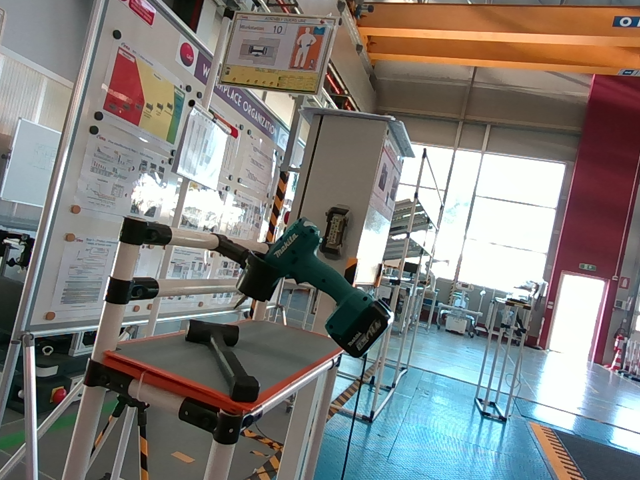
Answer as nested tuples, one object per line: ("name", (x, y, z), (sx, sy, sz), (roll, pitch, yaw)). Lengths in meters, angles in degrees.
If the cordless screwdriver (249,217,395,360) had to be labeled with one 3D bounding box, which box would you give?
("cordless screwdriver", (-0.003, 0.098, 0.727), (0.248, 0.159, 0.074), (46, 11, 14))
